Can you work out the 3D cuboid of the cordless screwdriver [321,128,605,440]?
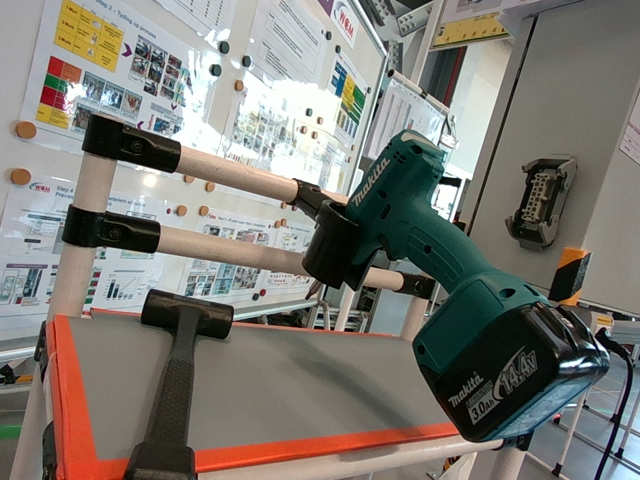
[{"bbox_3d":[0.082,0.036,0.352,0.074,0.160,0.249,12,38,-37],"label":"cordless screwdriver"}]
